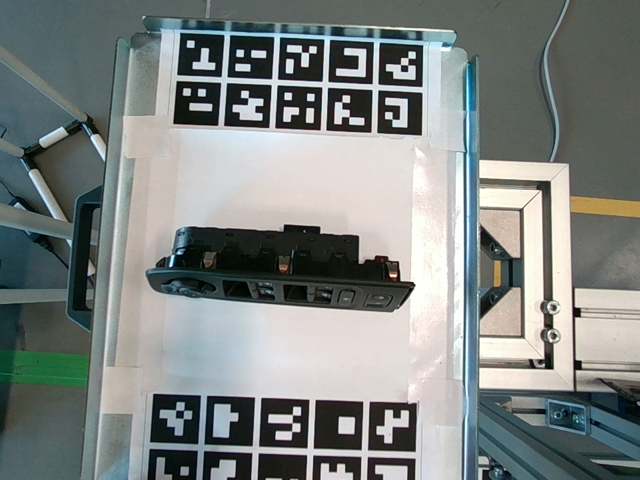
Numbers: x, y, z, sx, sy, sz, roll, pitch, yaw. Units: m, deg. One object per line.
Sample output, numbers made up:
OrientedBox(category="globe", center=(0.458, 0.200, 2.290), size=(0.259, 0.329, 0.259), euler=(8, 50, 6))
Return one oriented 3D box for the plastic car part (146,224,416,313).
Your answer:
OrientedBox(category="plastic car part", center=(-0.034, 0.019, 0.331), size=(0.203, 0.067, 0.066), euler=(0, -18, 1))
